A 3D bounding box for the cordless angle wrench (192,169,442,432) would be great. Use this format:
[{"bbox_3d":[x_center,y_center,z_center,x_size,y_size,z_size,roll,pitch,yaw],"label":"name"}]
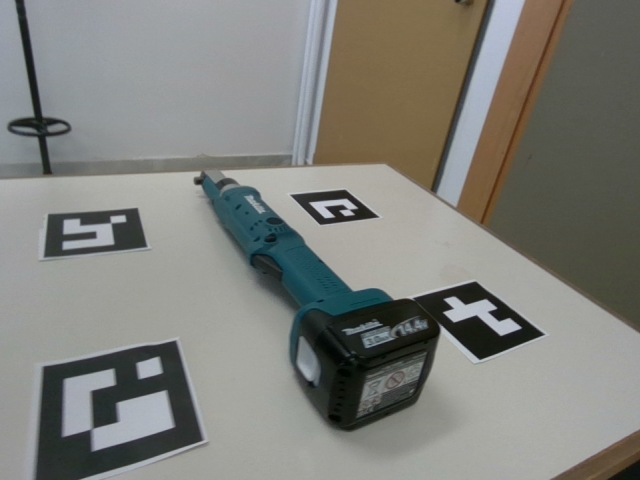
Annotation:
[{"bbox_3d":[-0.052,0.005,0.457,0.097,0.074,0.426,-9,32,-30],"label":"cordless angle wrench"}]
